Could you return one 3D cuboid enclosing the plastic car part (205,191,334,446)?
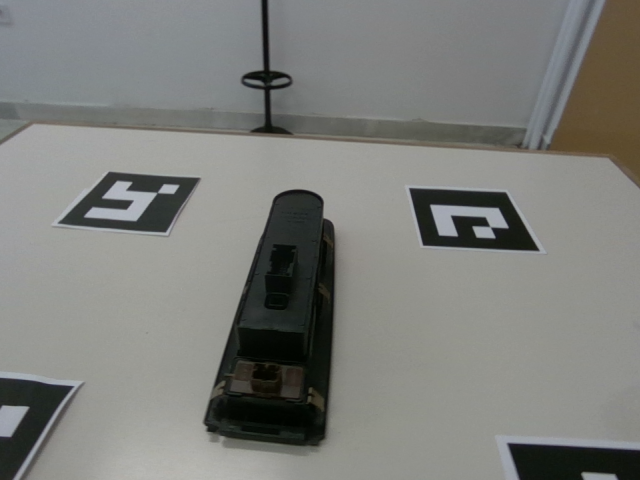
[{"bbox_3d":[-0.025,0.027,0.292,0.066,0.067,0.203,-3,33,7],"label":"plastic car part"}]
